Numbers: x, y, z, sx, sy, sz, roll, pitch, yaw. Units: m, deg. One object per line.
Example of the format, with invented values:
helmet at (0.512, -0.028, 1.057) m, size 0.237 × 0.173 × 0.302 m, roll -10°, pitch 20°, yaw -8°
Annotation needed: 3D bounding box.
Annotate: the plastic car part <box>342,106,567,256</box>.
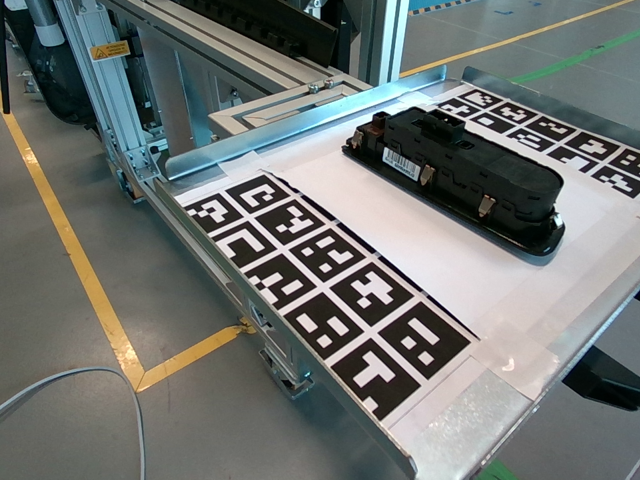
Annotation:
plastic car part at (0.113, -0.064, 0.355) m, size 0.066 × 0.067 × 0.203 m, roll -24°, pitch 52°, yaw -35°
